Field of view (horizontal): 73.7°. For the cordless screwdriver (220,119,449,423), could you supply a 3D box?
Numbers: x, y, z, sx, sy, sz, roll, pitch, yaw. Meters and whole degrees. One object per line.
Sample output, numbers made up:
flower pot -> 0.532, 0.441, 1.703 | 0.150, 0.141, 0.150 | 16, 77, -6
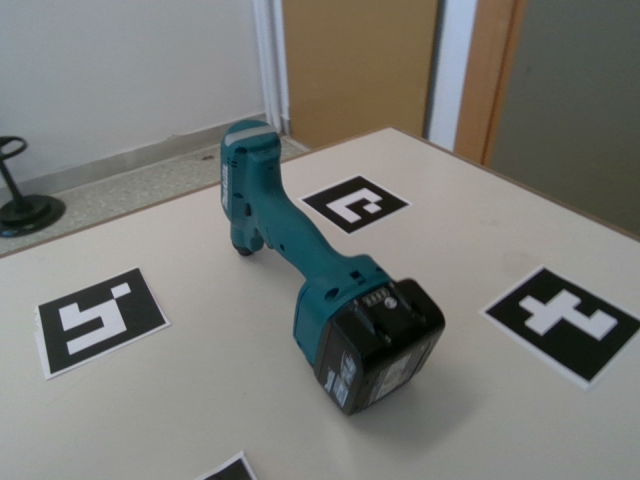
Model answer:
cordless screwdriver -> -0.017, 0.028, 0.366 | 0.074, 0.250, 0.159 | -20, -35, -27
